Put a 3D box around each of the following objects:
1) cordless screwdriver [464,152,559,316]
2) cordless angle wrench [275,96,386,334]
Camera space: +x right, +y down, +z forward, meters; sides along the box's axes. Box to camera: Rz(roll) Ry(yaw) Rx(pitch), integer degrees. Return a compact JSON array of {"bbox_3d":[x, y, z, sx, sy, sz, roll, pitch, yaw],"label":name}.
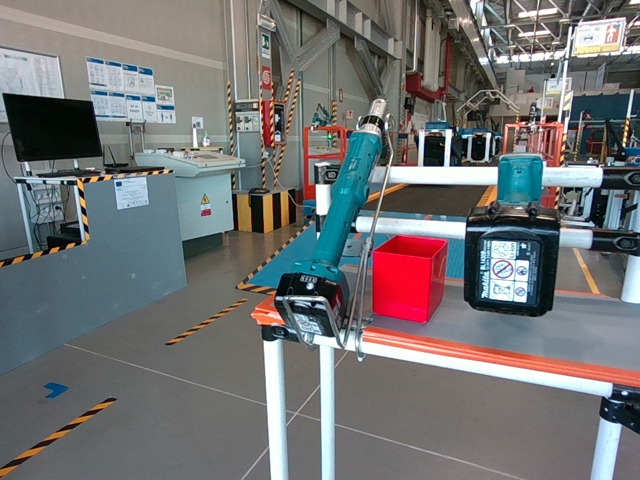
[{"bbox_3d":[0.214,0.004,0.467,0.074,0.159,0.248,3,23,26],"label":"cordless screwdriver"},{"bbox_3d":[0.043,-0.070,0.639,0.074,0.421,0.098,10,-30,17],"label":"cordless angle wrench"}]
